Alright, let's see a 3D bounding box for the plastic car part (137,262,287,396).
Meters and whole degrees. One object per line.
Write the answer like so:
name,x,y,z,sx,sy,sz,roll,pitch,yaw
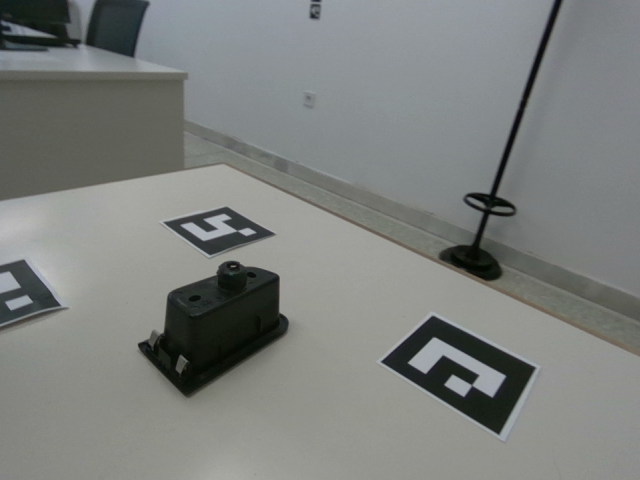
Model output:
plastic car part,-0.078,0.055,0.341,0.066,0.071,0.115,28,36,32
